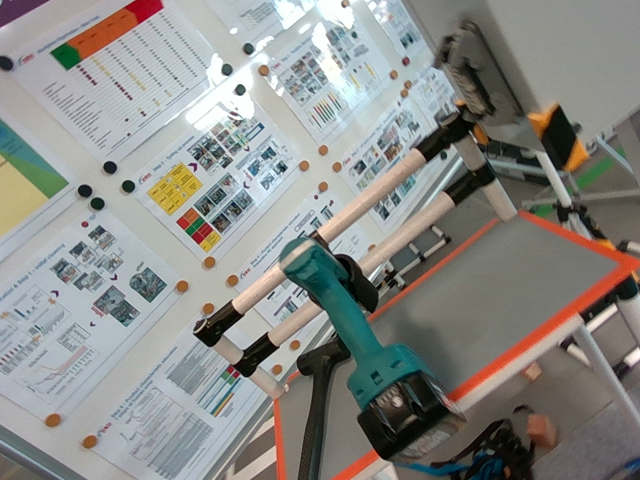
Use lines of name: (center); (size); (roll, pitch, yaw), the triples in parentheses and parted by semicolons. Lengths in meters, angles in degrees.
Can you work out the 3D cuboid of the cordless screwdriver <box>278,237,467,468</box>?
cordless screwdriver: (0.052, 0.113, 0.467); (0.074, 0.248, 0.159); (-40, -38, 6)
